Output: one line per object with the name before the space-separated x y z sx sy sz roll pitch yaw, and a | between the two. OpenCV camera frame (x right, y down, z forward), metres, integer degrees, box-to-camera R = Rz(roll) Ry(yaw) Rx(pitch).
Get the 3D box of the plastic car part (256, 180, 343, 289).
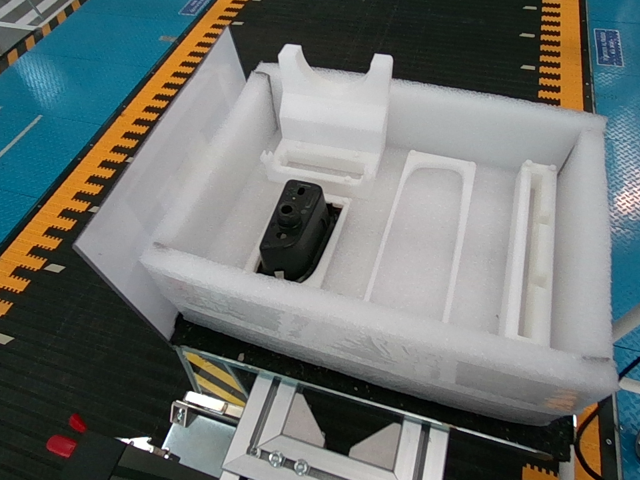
plastic car part | -0.026 -0.014 0.426 0.066 0.116 0.071 13 -35 15
